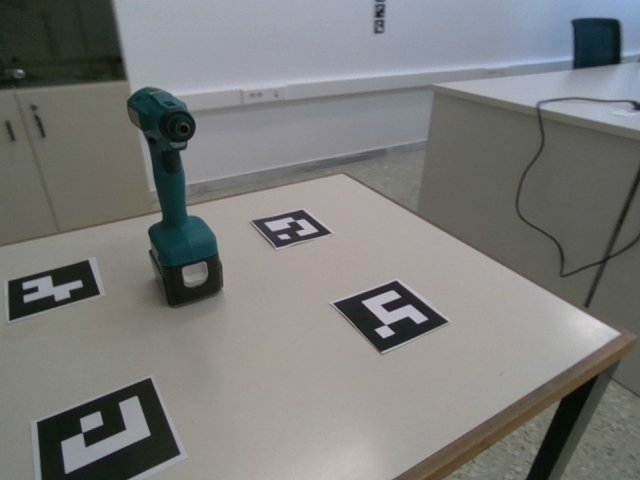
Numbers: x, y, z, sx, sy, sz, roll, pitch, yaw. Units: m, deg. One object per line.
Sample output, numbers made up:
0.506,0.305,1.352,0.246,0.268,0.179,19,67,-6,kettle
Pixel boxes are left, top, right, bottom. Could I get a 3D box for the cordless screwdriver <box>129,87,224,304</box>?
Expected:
-0.163,-0.042,0.494,0.074,0.248,0.160,-15,29,-26,cordless screwdriver
